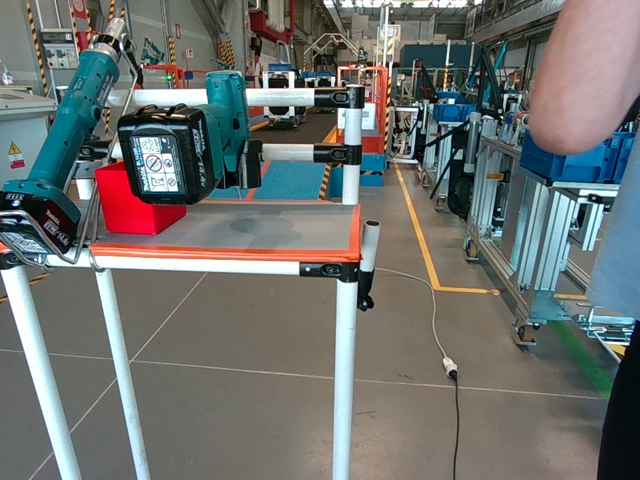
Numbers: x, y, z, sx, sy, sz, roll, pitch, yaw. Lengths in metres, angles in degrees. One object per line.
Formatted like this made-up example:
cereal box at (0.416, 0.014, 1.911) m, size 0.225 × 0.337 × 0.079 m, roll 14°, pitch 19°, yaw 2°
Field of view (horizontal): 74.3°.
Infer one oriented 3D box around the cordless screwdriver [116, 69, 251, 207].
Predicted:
cordless screwdriver at (-0.136, -0.107, 0.512) m, size 0.074 × 0.159 × 0.248 m, roll 1°, pitch 29°, yaw 7°

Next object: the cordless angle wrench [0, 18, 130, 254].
cordless angle wrench at (-0.357, -0.185, 0.628) m, size 0.074 × 0.421 × 0.098 m, roll 5°, pitch -27°, yaw -1°
